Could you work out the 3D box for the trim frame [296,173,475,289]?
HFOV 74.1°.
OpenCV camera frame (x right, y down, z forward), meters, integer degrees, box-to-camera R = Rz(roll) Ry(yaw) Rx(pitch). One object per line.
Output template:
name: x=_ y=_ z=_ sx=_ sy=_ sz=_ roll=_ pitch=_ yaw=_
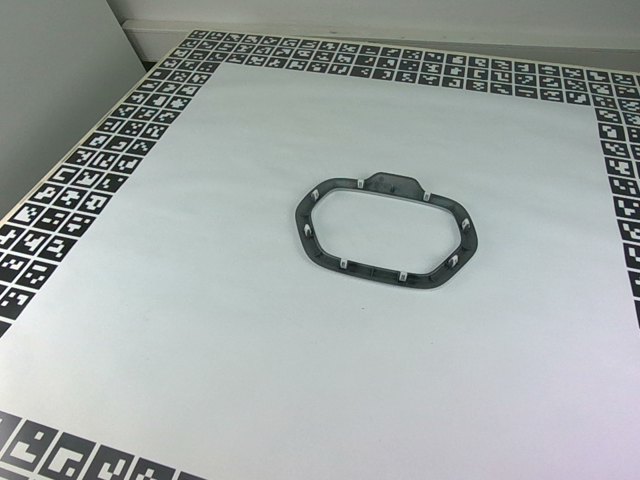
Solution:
trim frame: x=0.087 y=-0.021 z=0.587 sx=0.249 sy=0.183 sz=0.027 roll=11 pitch=-37 yaw=12
